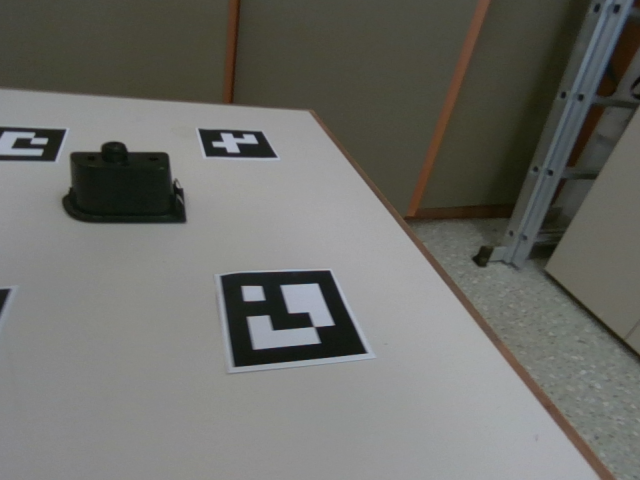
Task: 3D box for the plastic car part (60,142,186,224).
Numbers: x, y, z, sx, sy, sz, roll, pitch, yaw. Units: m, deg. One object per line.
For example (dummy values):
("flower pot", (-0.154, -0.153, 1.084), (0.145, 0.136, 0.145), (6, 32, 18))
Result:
("plastic car part", (-0.192, -0.059, 0.418), (0.115, 0.071, 0.066), (1, 34, -23))
